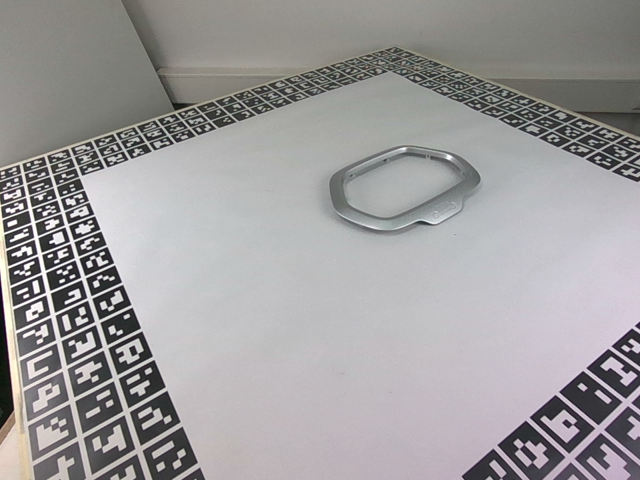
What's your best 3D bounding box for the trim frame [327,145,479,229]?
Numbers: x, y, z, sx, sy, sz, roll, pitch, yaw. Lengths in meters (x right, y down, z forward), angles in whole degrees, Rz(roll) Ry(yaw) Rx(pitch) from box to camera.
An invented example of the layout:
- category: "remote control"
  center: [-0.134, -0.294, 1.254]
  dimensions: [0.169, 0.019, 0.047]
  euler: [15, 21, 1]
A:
- category: "trim frame"
  center: [0.125, -0.087, 0.650]
  dimensions: [0.247, 0.027, 0.185]
  euler: [-25, 46, -26]
